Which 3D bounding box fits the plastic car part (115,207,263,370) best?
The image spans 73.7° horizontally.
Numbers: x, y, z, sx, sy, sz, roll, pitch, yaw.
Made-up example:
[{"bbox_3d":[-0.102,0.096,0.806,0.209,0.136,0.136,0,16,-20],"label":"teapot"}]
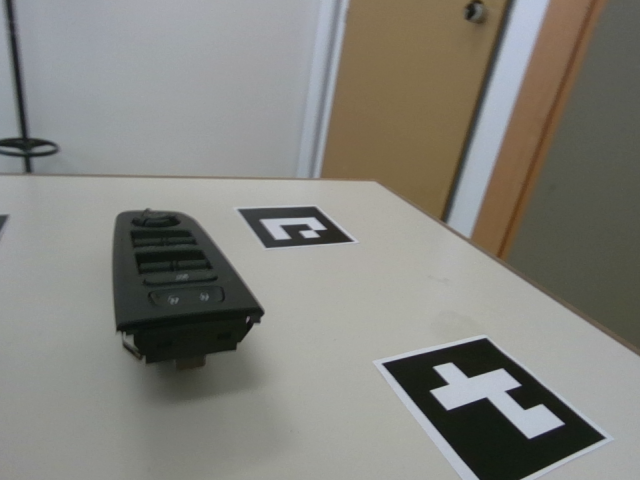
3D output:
[{"bbox_3d":[-0.098,0.025,0.287,0.066,0.067,0.204,-11,28,-22],"label":"plastic car part"}]
